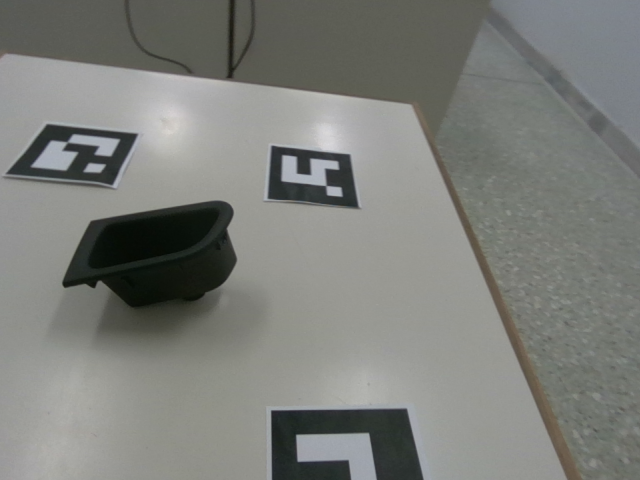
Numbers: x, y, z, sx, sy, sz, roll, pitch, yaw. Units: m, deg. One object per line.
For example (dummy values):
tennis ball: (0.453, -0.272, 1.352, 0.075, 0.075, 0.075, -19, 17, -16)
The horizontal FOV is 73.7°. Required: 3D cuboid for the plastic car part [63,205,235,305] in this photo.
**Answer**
plastic car part: (-0.118, 0.020, 0.331, 0.117, 0.066, 0.071, -6, -39, 6)
